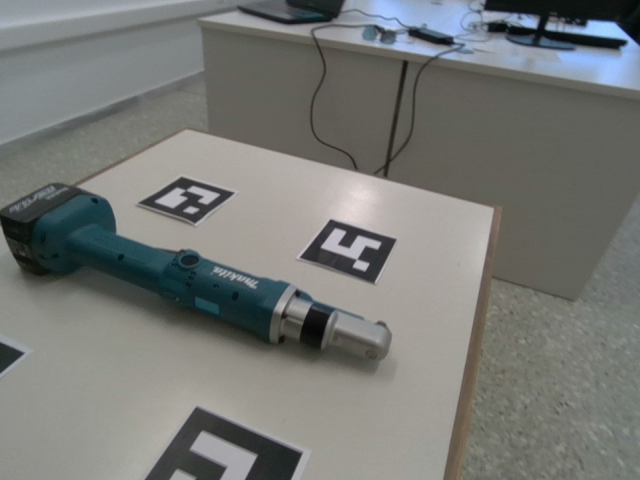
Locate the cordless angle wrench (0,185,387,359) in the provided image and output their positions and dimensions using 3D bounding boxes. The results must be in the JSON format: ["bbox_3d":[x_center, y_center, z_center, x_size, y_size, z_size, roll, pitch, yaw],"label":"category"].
[{"bbox_3d":[-0.137,0.042,0.453,0.425,0.074,0.097,17,35,12],"label":"cordless angle wrench"}]
